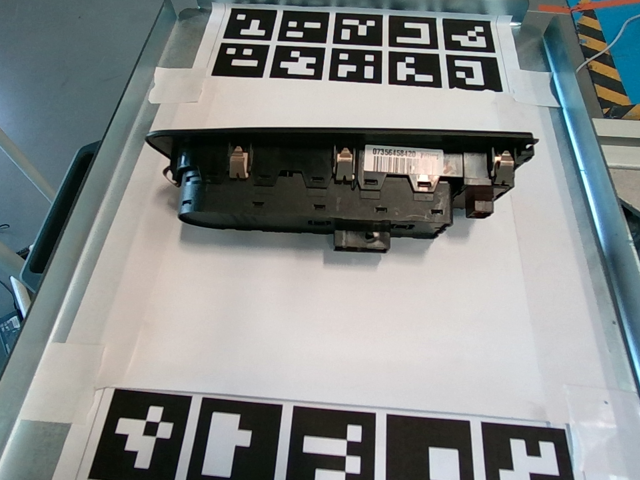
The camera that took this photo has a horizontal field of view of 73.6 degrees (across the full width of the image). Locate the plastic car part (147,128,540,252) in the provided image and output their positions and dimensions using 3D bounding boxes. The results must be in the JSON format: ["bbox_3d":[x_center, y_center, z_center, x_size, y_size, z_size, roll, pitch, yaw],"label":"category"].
[{"bbox_3d":[0.006,-0.028,0.243,0.203,0.067,0.066,6,-3,3],"label":"plastic car part"}]
